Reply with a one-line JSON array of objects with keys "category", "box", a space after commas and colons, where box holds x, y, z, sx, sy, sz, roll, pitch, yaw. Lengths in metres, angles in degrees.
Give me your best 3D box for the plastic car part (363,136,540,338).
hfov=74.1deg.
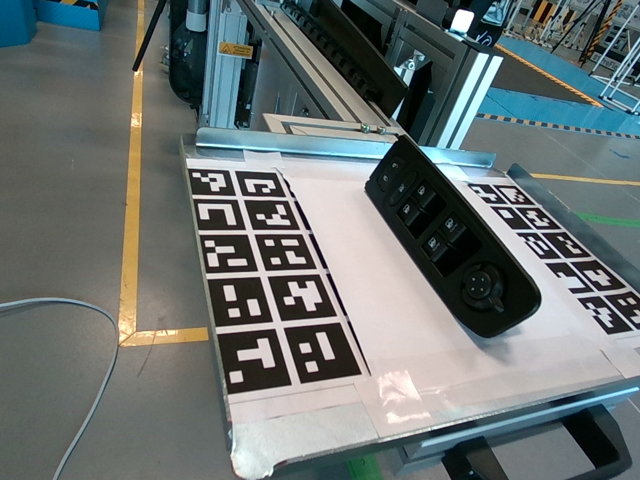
[{"category": "plastic car part", "box": [0.109, -0.003, 0.361, 0.067, 0.067, 0.203, 26, 27, -38]}]
